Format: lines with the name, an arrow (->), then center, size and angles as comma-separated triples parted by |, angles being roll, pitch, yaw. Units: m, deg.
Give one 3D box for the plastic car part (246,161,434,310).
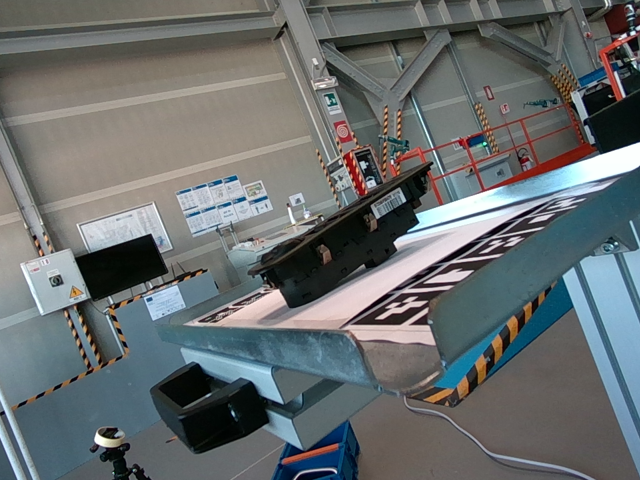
plastic car part -> 0.026, -0.002, 0.370 | 0.202, 0.067, 0.067 | -28, 12, -31
